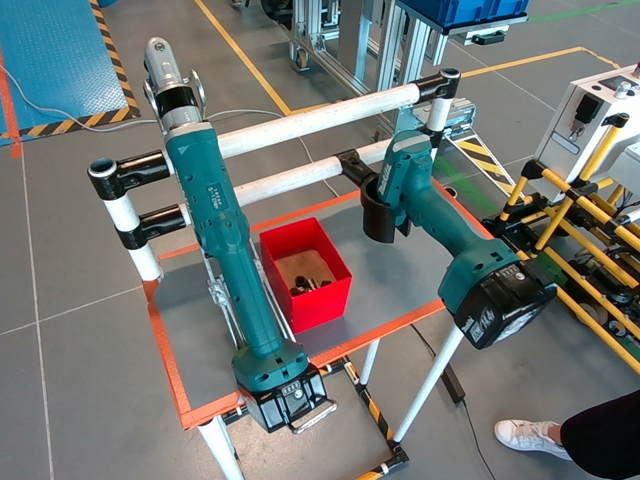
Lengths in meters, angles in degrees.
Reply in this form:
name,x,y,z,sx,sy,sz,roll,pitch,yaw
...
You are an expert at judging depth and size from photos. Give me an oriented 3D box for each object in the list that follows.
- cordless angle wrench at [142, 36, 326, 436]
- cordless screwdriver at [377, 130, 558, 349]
name,x,y,z,sx,sy,sz,roll,pitch,yaw
cordless angle wrench,-0.105,-0.008,0.454,0.074,0.423,0.098,-21,5,-28
cordless screwdriver,0.144,0.006,0.503,0.074,0.248,0.160,-21,-29,-17
